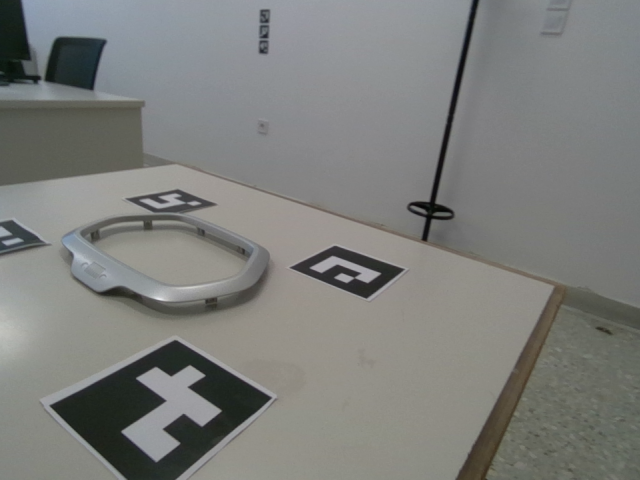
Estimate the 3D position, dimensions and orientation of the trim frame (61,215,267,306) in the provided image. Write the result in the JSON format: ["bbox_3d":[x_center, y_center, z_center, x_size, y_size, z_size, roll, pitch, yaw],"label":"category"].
[{"bbox_3d":[-0.174,0.015,0.479,0.251,0.027,0.182,22,25,31],"label":"trim frame"}]
